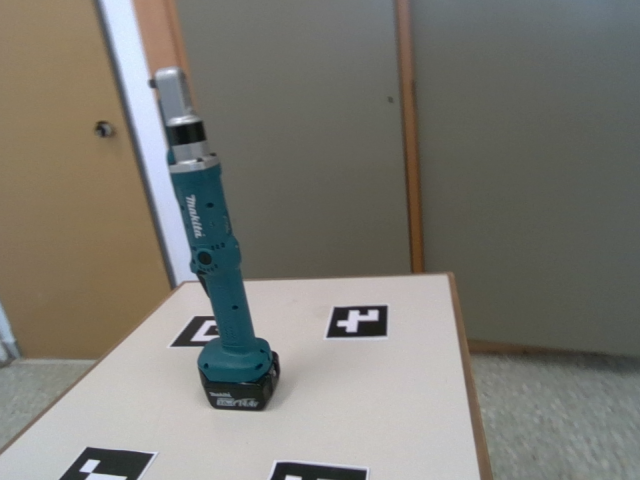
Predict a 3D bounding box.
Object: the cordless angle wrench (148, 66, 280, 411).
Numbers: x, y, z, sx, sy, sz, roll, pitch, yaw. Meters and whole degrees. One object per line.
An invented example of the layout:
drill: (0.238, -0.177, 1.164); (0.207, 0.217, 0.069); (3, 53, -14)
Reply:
cordless angle wrench: (-0.131, 0.013, 0.522); (0.098, 0.422, 0.074); (-4, 19, 14)
